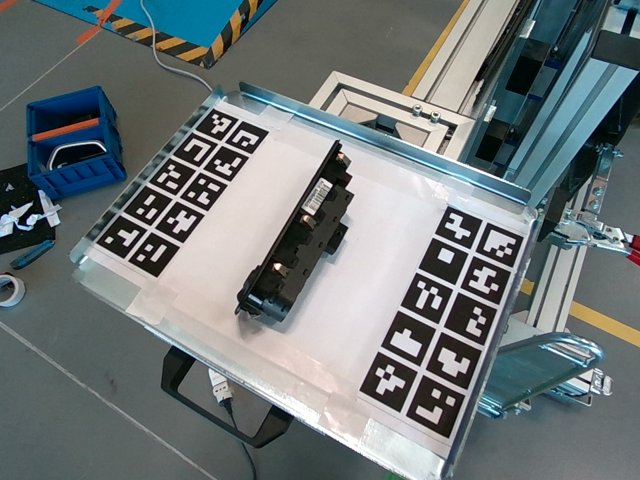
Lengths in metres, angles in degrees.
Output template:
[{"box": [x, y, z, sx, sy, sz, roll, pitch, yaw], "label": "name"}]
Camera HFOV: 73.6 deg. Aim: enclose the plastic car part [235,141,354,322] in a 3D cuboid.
[{"box": [-0.017, -0.001, 0.426, 0.067, 0.202, 0.067, 38, -25, -10], "label": "plastic car part"}]
